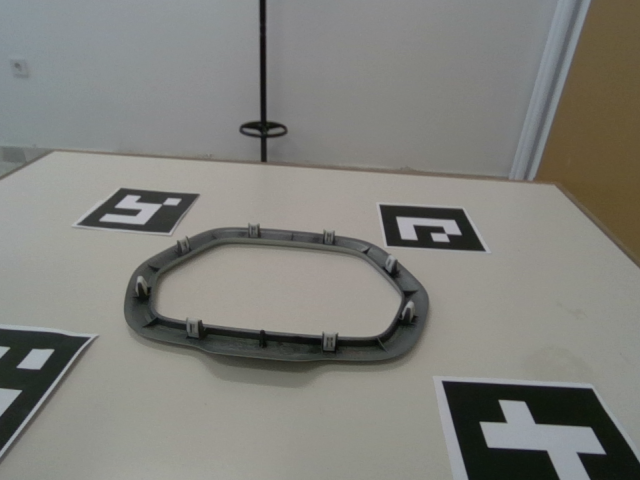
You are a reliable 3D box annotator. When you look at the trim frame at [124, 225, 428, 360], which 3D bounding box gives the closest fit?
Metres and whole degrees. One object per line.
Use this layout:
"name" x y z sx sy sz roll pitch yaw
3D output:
"trim frame" -0.035 0.035 0.358 0.249 0.027 0.184 6 31 4
